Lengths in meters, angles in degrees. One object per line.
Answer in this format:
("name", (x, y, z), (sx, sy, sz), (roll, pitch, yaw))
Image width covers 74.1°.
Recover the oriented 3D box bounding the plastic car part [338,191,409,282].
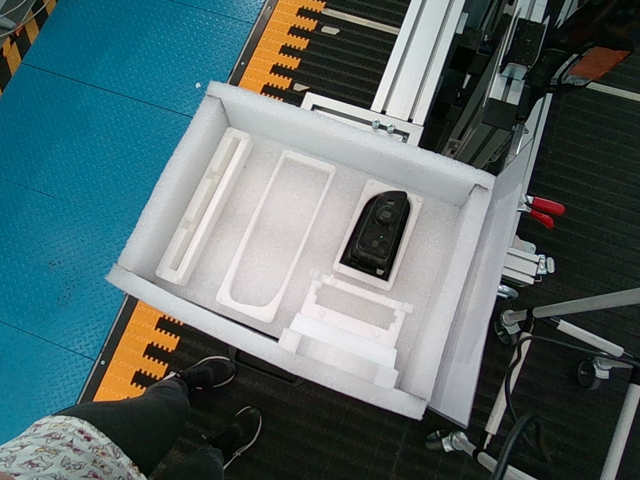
("plastic car part", (0.074, -0.016, 0.527), (0.066, 0.116, 0.071), (22, -10, 6))
